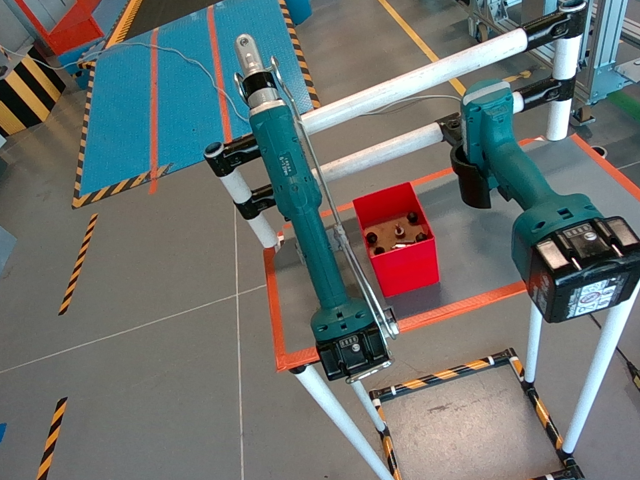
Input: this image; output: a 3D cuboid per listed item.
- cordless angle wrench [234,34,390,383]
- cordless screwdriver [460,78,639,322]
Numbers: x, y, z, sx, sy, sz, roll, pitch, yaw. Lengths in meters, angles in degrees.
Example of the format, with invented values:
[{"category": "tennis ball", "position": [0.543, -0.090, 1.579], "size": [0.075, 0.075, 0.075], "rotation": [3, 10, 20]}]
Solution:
[{"category": "cordless angle wrench", "position": [-0.026, -0.051, 0.506], "size": [0.074, 0.422, 0.098], "rotation": [-19, -4, -1]}, {"category": "cordless screwdriver", "position": [0.217, -0.037, 0.447], "size": [0.074, 0.248, 0.159], "rotation": [-20, -35, 9]}]
